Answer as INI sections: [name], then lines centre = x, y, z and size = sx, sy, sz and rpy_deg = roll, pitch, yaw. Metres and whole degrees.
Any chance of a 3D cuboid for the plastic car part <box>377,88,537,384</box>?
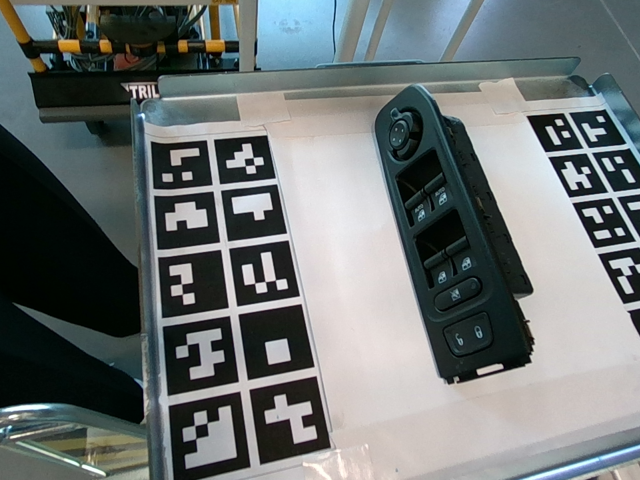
[plastic car part]
centre = 0.091, -0.017, 0.283
size = 0.067, 0.203, 0.066
rpy_deg = -8, -24, -18
